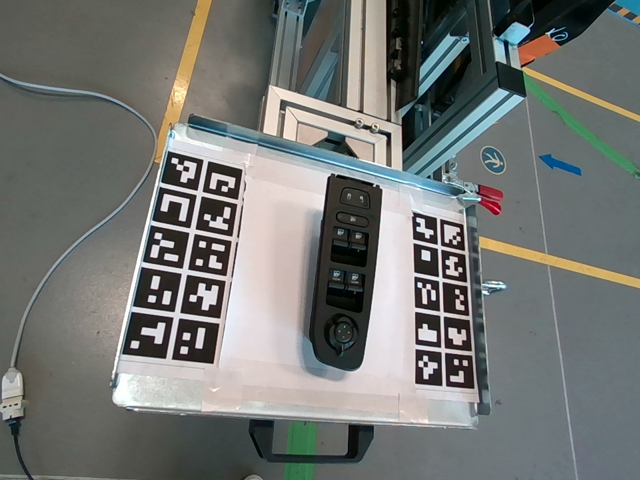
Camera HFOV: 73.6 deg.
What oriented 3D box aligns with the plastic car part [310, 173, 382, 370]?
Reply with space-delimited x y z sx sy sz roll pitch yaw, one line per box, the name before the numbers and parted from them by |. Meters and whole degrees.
plastic car part | 0.019 0.035 0.464 0.066 0.202 0.067 13 -19 -26
